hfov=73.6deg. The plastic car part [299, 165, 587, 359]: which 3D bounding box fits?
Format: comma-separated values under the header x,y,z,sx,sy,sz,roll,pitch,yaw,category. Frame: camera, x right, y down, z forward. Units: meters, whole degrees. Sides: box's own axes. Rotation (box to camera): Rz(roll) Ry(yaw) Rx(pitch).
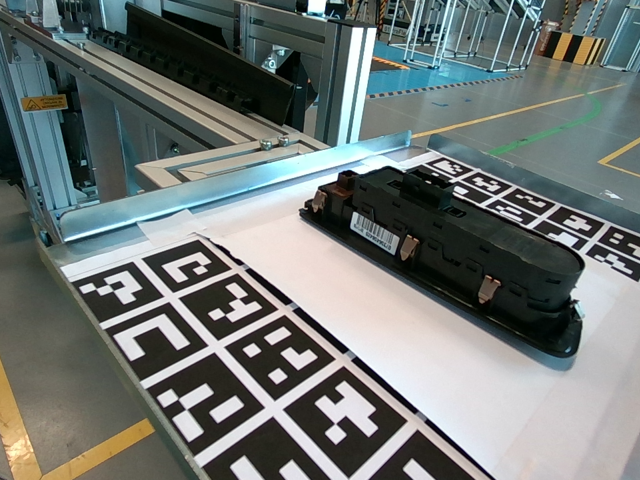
x,y,z,sx,sy,sz,roll,pitch,yaw,category
0.080,-0.004,0.284,0.204,0.067,0.066,36,35,31,plastic car part
